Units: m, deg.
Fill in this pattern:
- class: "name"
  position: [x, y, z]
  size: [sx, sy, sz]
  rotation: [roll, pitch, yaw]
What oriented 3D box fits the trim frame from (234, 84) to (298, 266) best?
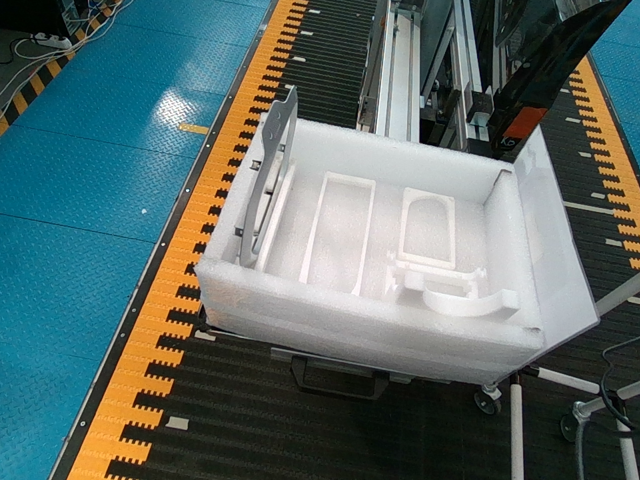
- class: "trim frame"
  position: [-0.063, -0.079, 0.525]
  size: [0.027, 0.247, 0.185]
  rotation: [16, -33, -1]
